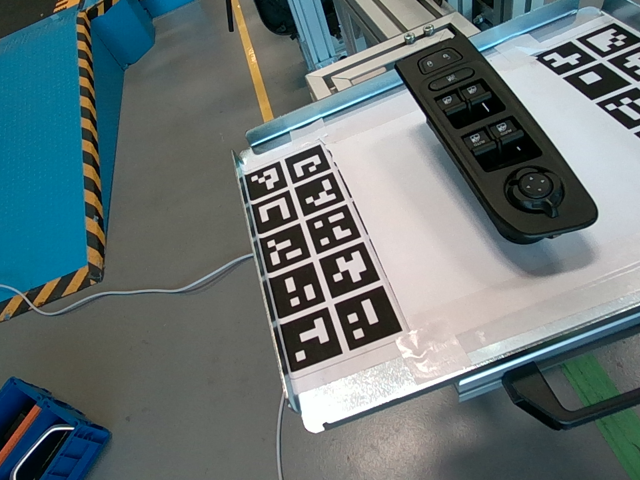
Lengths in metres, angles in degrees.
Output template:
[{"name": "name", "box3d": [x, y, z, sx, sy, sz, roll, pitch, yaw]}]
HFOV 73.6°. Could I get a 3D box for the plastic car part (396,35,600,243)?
[{"name": "plastic car part", "box3d": [0.127, -0.075, 0.337, 0.066, 0.203, 0.067, -18, -35, -4]}]
